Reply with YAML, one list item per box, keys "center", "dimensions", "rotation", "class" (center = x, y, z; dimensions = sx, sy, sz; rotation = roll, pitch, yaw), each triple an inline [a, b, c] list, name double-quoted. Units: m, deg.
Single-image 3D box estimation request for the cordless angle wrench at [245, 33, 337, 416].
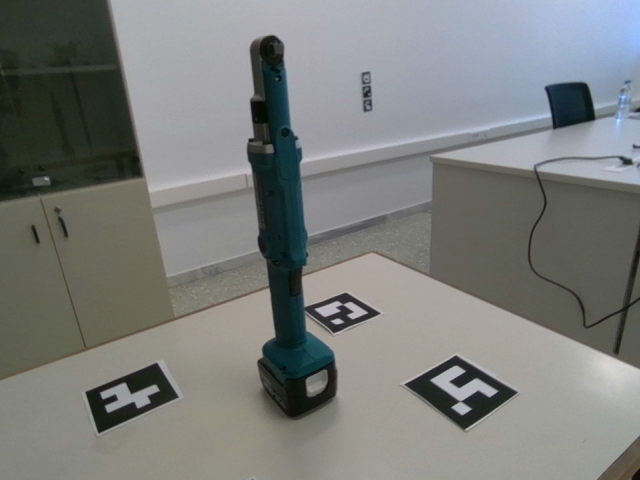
- center: [-0.042, 0.001, 0.483]
  dimensions: [0.074, 0.422, 0.099]
  rotation: [-17, 25, -31]
  class: "cordless angle wrench"
